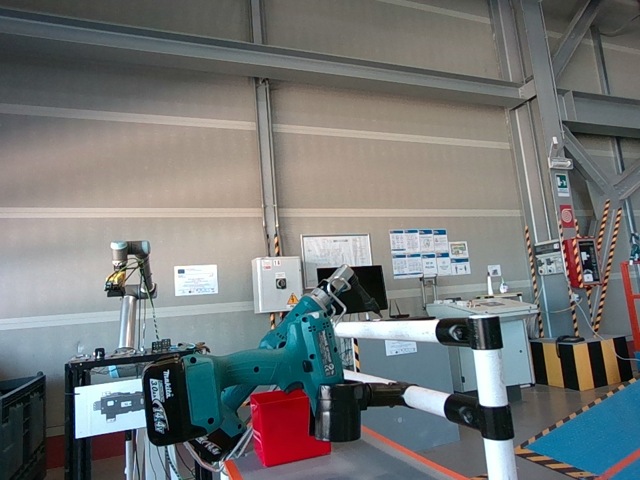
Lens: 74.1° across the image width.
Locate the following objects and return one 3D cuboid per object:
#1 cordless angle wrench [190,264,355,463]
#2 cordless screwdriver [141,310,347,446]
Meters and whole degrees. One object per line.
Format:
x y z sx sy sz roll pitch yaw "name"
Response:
-0.076 0.196 0.782 0.422 0.098 0.074 -47 13 -22 "cordless angle wrench"
-0.085 0.192 0.529 0.248 0.159 0.074 -10 -10 -22 "cordless screwdriver"
